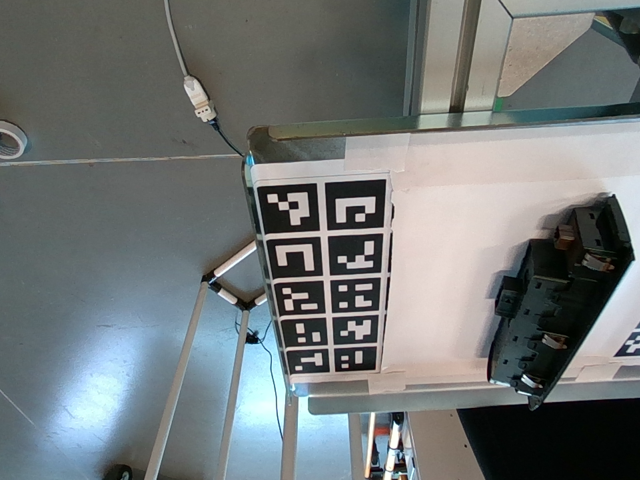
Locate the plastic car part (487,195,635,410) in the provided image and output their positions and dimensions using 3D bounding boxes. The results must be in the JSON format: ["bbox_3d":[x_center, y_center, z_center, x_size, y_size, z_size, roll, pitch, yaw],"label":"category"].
[{"bbox_3d":[0.171,0.064,0.334,0.067,0.203,0.066,2,41,12],"label":"plastic car part"}]
